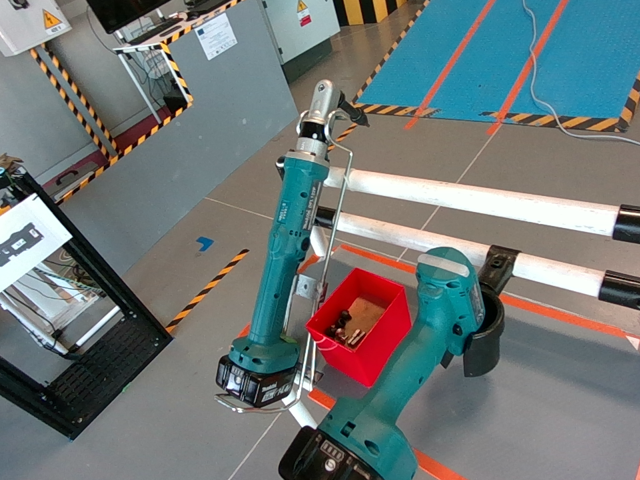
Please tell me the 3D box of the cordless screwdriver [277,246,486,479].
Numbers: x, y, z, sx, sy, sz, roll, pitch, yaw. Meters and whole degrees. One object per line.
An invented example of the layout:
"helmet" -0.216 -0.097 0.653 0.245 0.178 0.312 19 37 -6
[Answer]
"cordless screwdriver" 0.082 0.142 0.392 0.074 0.248 0.159 19 -28 40

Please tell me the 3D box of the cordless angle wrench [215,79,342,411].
"cordless angle wrench" -0.038 0.001 0.552 0.074 0.423 0.098 16 4 33
